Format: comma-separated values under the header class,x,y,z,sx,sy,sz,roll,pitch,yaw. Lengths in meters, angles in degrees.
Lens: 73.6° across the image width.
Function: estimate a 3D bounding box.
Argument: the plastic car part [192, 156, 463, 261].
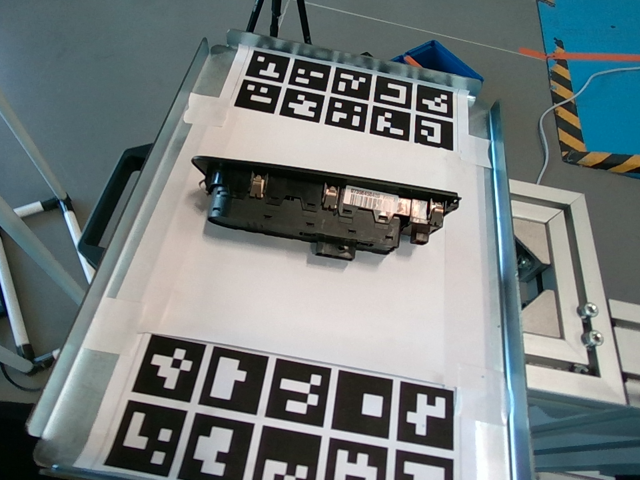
class,x,y,z,sx,sy,sz,roll,pitch,yaw
plastic car part,-0.002,-0.022,0.338,0.203,0.067,0.066,14,-3,0
